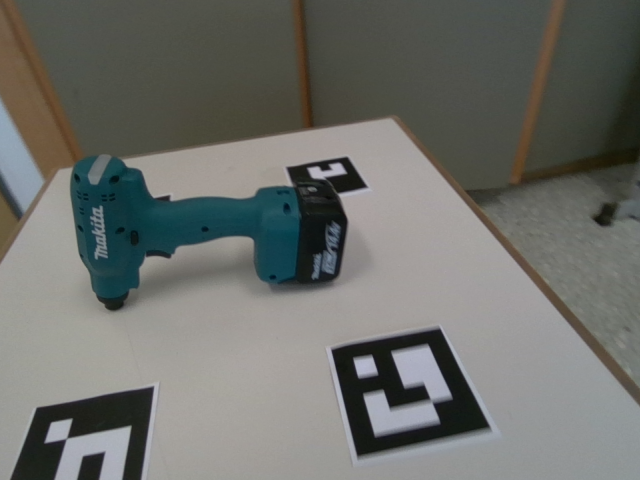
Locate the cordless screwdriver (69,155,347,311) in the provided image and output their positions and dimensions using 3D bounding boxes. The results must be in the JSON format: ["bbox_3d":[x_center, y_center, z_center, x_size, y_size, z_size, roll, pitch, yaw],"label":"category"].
[{"bbox_3d":[-0.104,0.007,0.423,0.247,0.159,0.074,3,32,-12],"label":"cordless screwdriver"}]
